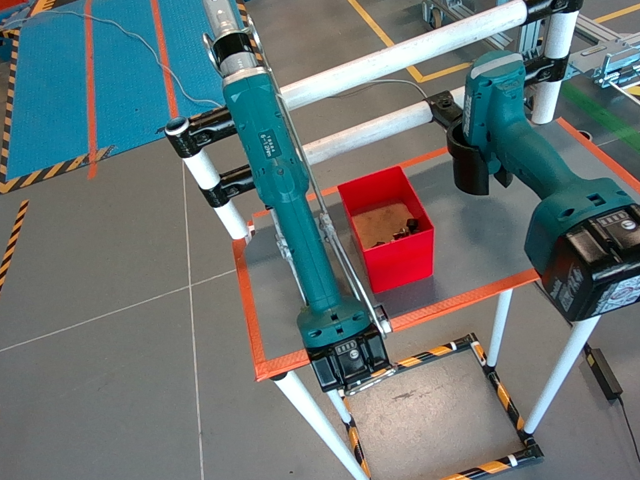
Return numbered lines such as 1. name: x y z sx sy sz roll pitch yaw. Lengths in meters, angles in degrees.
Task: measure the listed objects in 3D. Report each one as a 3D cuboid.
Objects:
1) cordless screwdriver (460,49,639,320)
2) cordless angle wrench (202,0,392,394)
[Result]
1. cordless screwdriver: 0.206 -0.046 0.406 0.074 0.248 0.159 -19 -33 2
2. cordless angle wrench: -0.040 -0.061 0.439 0.074 0.422 0.098 -20 -1 -5
